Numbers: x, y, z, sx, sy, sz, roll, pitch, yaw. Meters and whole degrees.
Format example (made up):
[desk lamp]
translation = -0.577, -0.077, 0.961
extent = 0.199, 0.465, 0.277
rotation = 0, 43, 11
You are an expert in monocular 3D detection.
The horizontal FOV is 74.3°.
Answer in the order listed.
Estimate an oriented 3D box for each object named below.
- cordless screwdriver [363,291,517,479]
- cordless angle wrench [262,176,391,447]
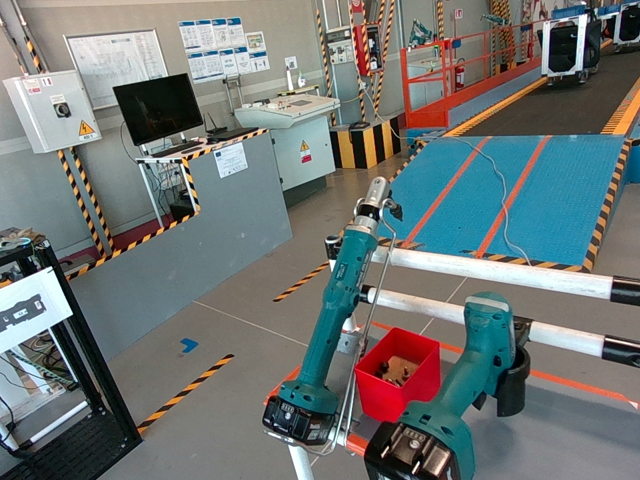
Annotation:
[cordless screwdriver]
translation = 0.154, 0.190, 0.465
extent = 0.074, 0.159, 0.248
rotation = 10, 40, 42
[cordless angle wrench]
translation = 0.034, 0.090, 0.654
extent = 0.074, 0.422, 0.098
rotation = 12, -16, 33
